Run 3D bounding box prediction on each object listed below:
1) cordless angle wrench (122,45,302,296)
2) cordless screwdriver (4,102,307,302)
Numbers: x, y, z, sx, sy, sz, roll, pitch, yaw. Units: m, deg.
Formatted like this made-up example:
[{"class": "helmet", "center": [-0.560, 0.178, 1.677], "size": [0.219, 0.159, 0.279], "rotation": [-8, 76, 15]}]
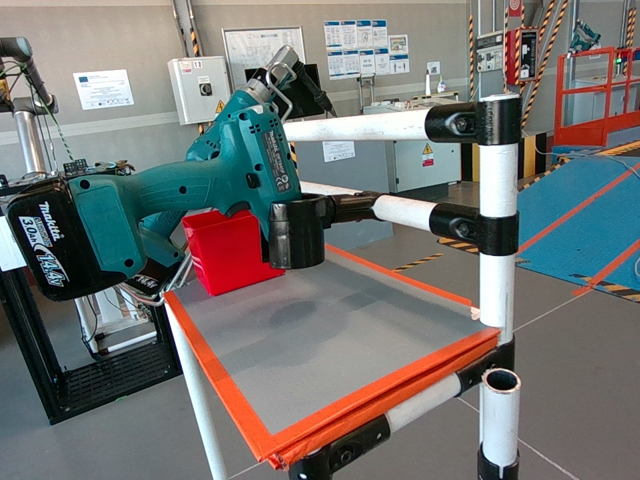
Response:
[{"class": "cordless angle wrench", "center": [-0.158, -0.120, 0.620], "size": [0.098, 0.422, 0.074], "rotation": [40, -10, -38]}, {"class": "cordless screwdriver", "center": [-0.129, -0.018, 0.397], "size": [0.248, 0.159, 0.074], "rotation": [-25, 21, -23]}]
